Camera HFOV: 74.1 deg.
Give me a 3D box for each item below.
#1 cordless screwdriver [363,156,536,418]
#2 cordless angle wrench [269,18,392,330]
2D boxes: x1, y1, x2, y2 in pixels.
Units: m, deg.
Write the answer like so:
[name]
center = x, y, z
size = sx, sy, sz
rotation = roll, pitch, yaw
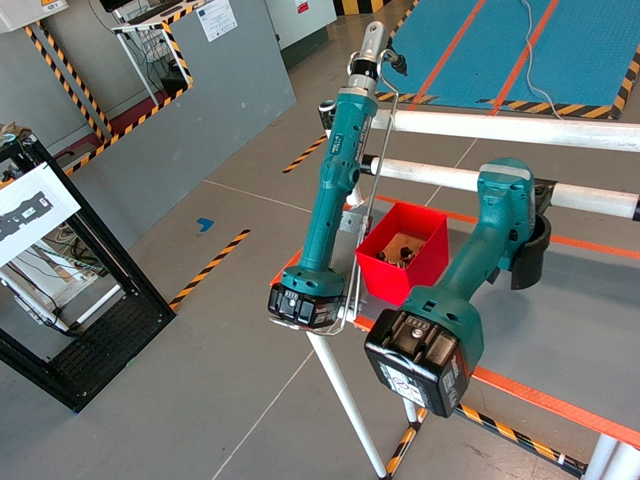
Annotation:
[cordless screwdriver]
center = 0.152, 0.053, 0.430
size = 0.074, 0.248, 0.159
rotation = 19, -28, 39
[cordless angle wrench]
center = 0.029, -0.091, 0.584
size = 0.074, 0.422, 0.098
rotation = 17, 5, 36
